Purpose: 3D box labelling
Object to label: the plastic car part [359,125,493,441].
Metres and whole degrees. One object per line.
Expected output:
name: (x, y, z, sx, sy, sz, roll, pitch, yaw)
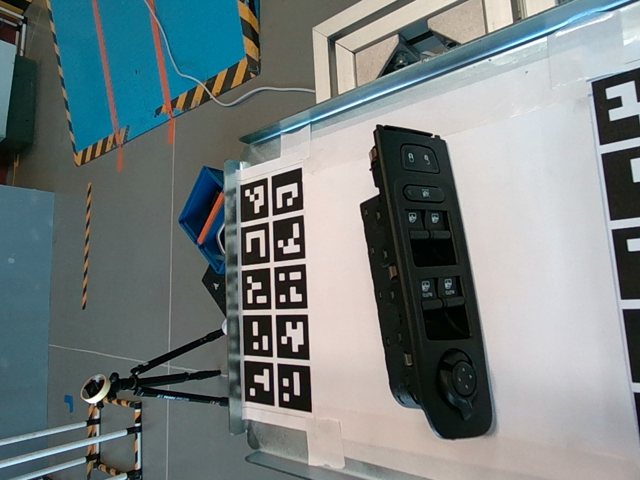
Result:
plastic car part: (0.063, 0.029, 0.288, 0.066, 0.202, 0.067, 1, -18, -40)
